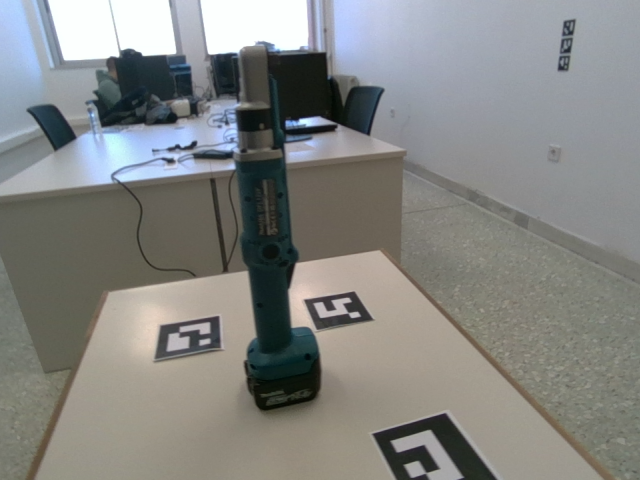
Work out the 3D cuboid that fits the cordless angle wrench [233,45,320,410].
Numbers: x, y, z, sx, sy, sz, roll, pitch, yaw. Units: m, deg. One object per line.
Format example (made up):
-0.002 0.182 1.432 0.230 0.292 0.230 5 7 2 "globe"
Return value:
-0.061 0.004 0.500 0.097 0.422 0.075 -8 23 -13 "cordless angle wrench"
